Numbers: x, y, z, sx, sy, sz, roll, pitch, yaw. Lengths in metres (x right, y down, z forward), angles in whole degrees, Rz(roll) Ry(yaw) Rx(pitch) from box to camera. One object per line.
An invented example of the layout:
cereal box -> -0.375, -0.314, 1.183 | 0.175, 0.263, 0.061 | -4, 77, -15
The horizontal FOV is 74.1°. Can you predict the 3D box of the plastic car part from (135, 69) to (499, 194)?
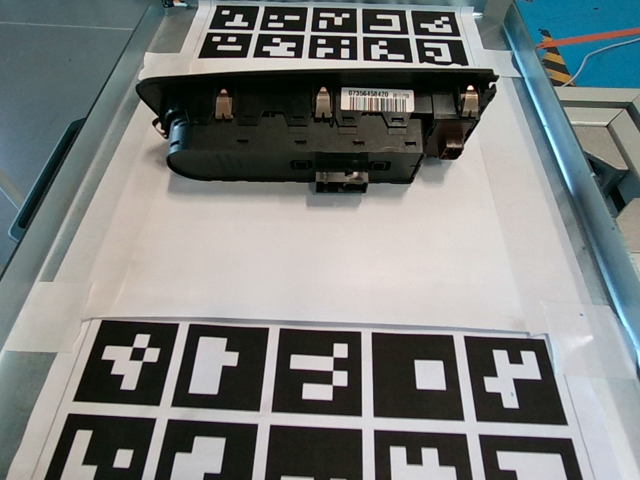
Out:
plastic car part -> -0.006, -0.062, 0.256 | 0.203, 0.067, 0.066 | 4, -8, 1
